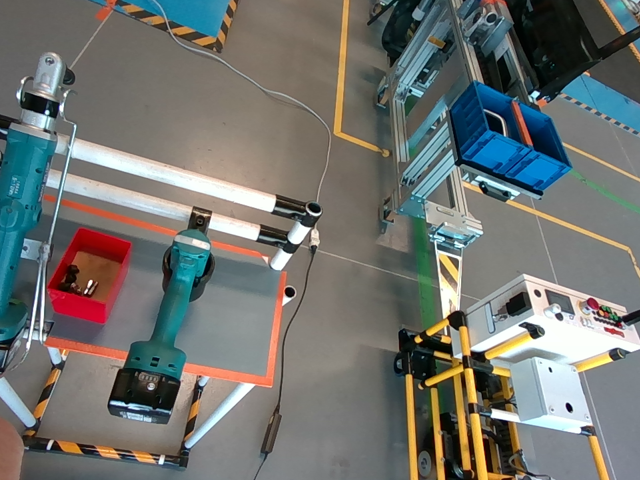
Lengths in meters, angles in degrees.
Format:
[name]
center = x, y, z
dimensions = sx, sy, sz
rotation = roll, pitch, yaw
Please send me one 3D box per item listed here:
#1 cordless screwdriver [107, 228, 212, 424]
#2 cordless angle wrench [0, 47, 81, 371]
[cordless screwdriver]
center = -0.213, 0.119, 0.592
dimensions = 0.074, 0.248, 0.160
rotation = 17, -28, -15
[cordless angle wrench]
center = -0.382, -0.039, 0.575
dimensions = 0.074, 0.423, 0.098
rotation = 12, 10, 24
